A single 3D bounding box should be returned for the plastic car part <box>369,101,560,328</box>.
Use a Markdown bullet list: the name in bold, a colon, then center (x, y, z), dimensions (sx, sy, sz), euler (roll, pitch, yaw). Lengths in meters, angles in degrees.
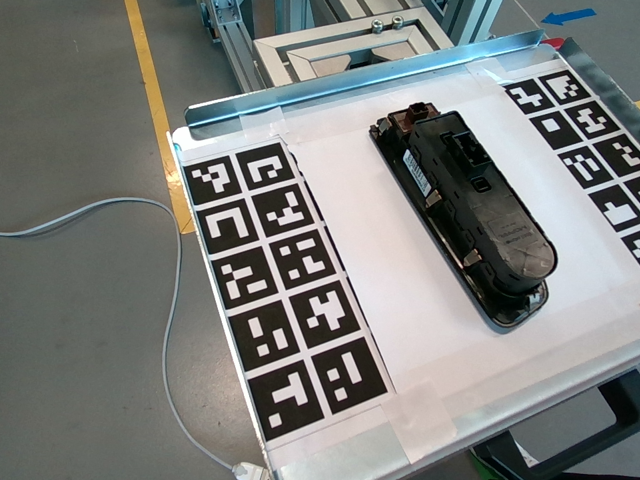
- **plastic car part**: center (0.115, -0.036, 0.327), dimensions (0.066, 0.203, 0.067), euler (-16, -22, -19)
